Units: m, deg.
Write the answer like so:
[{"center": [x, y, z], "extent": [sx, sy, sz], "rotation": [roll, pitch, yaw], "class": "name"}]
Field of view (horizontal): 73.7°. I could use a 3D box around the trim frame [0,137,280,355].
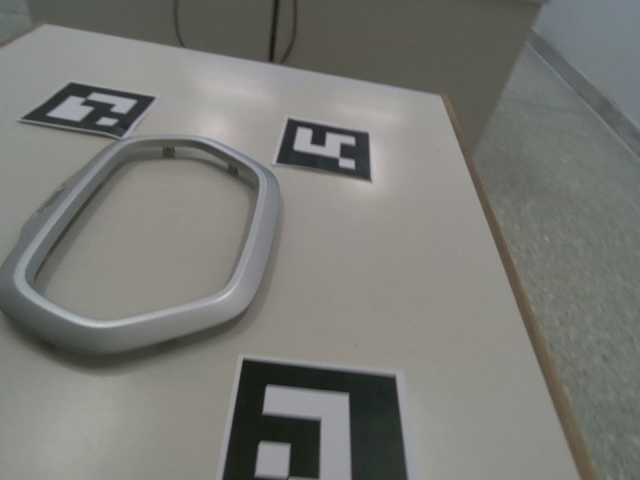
[{"center": [-0.127, -0.017, 0.332], "extent": [0.184, 0.027, 0.248], "rotation": [9, 43, -4], "class": "trim frame"}]
